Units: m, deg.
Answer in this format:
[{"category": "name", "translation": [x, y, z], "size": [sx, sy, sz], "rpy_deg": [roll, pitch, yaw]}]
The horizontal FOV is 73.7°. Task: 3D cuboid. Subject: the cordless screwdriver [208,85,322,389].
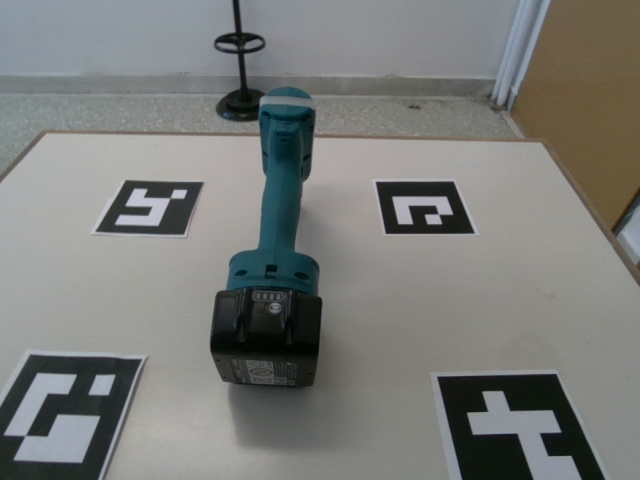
[{"category": "cordless screwdriver", "translation": [-0.037, 0.003, 0.386], "size": [0.074, 0.248, 0.159], "rpy_deg": [4, -31, -2]}]
